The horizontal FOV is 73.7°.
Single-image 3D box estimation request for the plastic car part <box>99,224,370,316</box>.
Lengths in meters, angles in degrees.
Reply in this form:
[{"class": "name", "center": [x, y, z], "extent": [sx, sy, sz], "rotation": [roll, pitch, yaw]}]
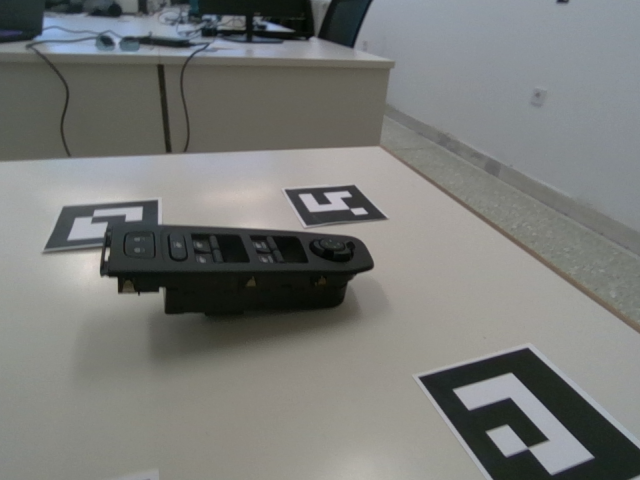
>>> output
[{"class": "plastic car part", "center": [-0.055, 0.026, 0.329], "extent": [0.201, 0.067, 0.067], "rotation": [-2, 21, -21]}]
